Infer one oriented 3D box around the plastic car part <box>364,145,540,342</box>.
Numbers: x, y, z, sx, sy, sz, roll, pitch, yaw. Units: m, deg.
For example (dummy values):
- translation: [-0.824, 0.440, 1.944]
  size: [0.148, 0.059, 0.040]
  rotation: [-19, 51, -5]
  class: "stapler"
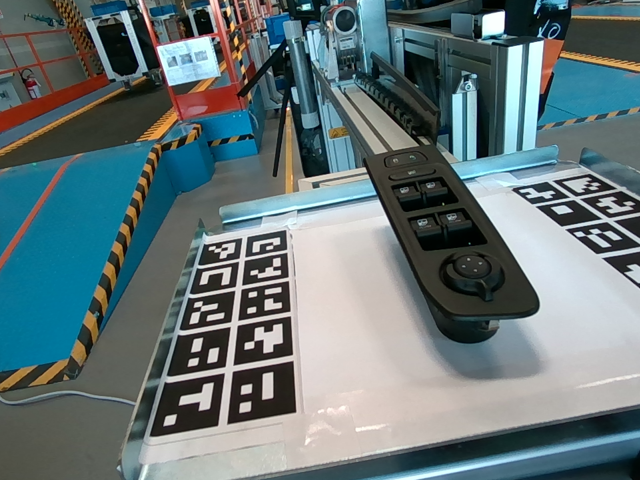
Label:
- translation: [0.083, -0.002, 0.319]
  size: [0.066, 0.067, 0.203]
  rotation: [-5, 34, -5]
  class: "plastic car part"
